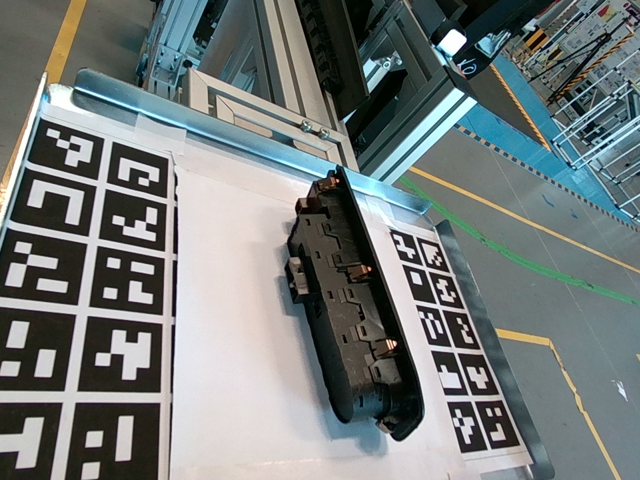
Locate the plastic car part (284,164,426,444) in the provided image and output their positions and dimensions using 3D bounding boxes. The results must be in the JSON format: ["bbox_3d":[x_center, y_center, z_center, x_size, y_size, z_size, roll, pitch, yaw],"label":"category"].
[{"bbox_3d":[0.015,0.040,0.305,0.067,0.203,0.067,-4,-31,-31],"label":"plastic car part"}]
